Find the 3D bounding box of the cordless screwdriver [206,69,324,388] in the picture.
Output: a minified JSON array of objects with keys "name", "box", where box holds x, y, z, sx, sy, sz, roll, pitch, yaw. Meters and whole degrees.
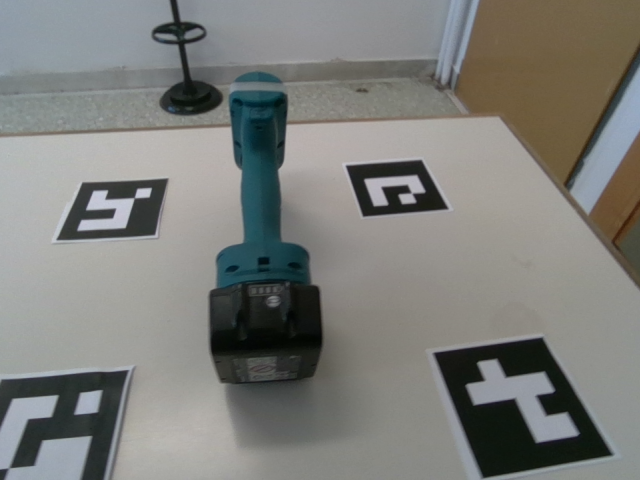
[{"name":"cordless screwdriver","box":[-0.051,-0.003,0.370,0.074,0.249,0.159,-1,-30,-8]}]
